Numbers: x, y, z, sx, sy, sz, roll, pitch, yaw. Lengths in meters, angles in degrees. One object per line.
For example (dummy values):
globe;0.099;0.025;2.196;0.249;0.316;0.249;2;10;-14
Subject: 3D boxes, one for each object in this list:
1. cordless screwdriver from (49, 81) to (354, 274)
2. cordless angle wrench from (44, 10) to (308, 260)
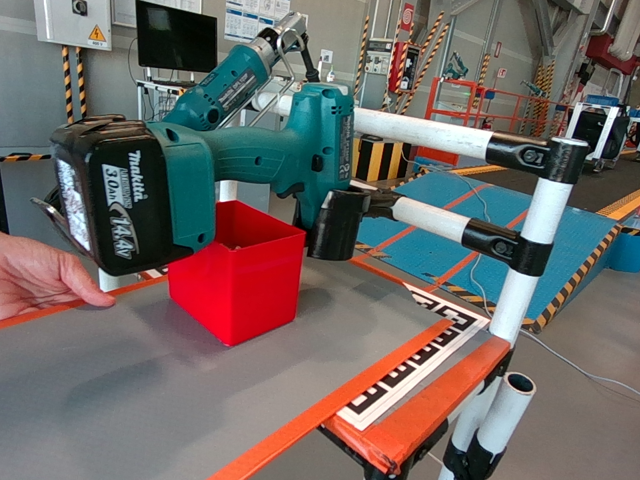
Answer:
cordless screwdriver;-0.067;-0.039;0.350;0.248;0.159;0.074;-23;34;-38
cordless angle wrench;-0.154;-0.163;0.549;0.074;0.422;0.098;27;-19;35
